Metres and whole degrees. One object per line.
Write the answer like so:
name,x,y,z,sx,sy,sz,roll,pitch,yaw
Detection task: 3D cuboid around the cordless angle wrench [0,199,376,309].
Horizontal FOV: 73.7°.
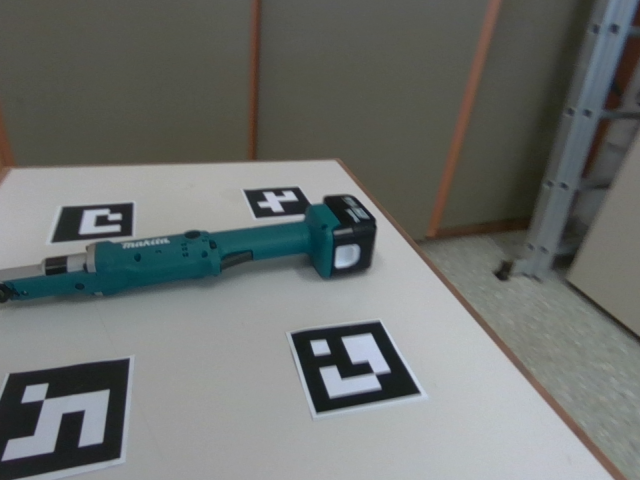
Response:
cordless angle wrench,-0.143,0.024,0.495,0.420,0.074,0.098,-8,35,-17
